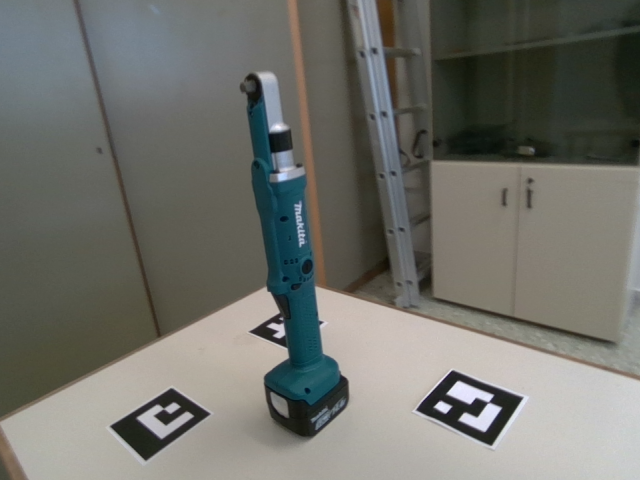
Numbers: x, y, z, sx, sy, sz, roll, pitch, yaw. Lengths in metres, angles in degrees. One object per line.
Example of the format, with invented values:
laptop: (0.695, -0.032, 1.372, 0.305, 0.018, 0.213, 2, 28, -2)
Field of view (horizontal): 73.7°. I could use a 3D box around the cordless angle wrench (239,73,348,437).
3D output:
cordless angle wrench: (-0.037, 0.029, 0.501, 0.075, 0.422, 0.097, 11, 25, 42)
